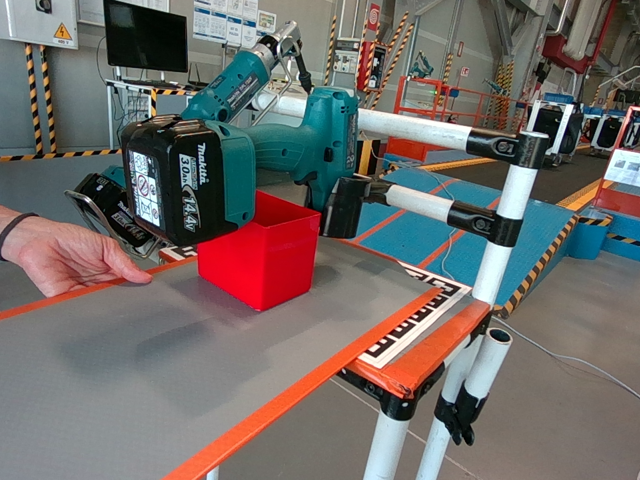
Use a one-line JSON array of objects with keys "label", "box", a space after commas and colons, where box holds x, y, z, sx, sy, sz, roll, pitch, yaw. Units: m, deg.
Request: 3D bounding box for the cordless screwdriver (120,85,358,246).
[{"label": "cordless screwdriver", "box": [-0.051, -0.057, 0.412, 0.074, 0.159, 0.248, 21, 33, 37]}]

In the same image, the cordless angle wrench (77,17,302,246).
[{"label": "cordless angle wrench", "box": [-0.157, -0.182, 0.607, 0.074, 0.422, 0.098, 27, -19, 28]}]
